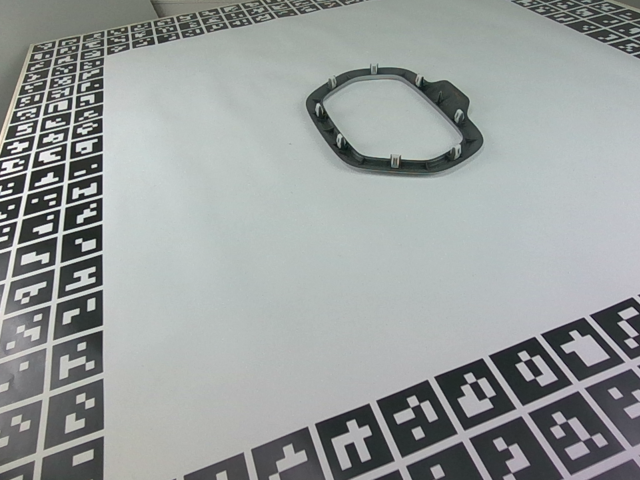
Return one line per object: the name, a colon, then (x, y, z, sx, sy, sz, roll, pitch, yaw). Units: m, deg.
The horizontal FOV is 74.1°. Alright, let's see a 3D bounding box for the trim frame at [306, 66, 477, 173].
trim frame: (0.084, -0.160, 0.532, 0.184, 0.027, 0.248, -16, 45, -8)
